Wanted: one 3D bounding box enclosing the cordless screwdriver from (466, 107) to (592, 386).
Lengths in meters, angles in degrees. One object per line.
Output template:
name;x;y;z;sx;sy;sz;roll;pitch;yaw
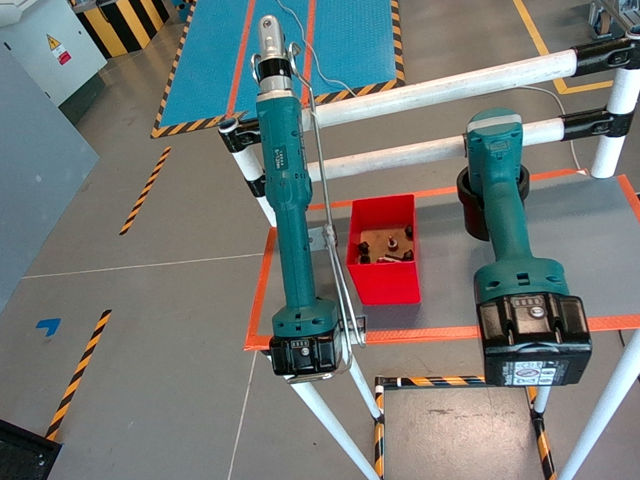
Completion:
cordless screwdriver;0.183;0.012;0.410;0.074;0.248;0.159;-6;-33;18

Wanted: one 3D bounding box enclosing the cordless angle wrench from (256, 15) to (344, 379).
cordless angle wrench;-0.036;-0.058;0.503;0.074;0.422;0.098;-7;-2;9
